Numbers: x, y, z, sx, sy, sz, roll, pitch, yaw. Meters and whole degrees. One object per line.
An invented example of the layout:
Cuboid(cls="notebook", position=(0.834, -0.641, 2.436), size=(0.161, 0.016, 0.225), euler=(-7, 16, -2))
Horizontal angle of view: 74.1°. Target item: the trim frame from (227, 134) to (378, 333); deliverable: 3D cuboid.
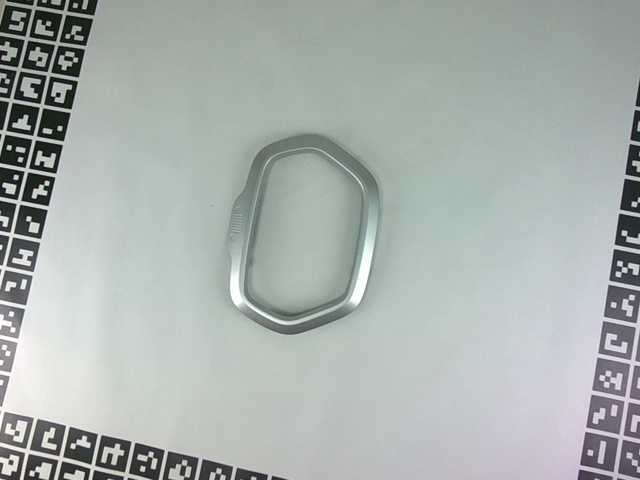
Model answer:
Cuboid(cls="trim frame", position=(-0.026, -0.009, 0.524), size=(0.184, 0.248, 0.027), euler=(8, 1, 5))
